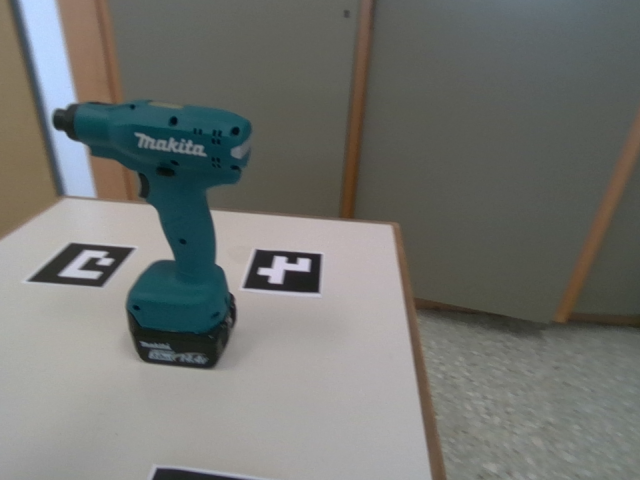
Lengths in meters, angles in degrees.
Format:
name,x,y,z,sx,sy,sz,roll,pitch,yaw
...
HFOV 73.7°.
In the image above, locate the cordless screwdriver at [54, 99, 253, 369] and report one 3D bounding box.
name,x,y,z,sx,sy,sz,roll,pitch,yaw
cordless screwdriver,-0.149,-0.002,0.396,0.159,0.249,0.074,9,28,3
